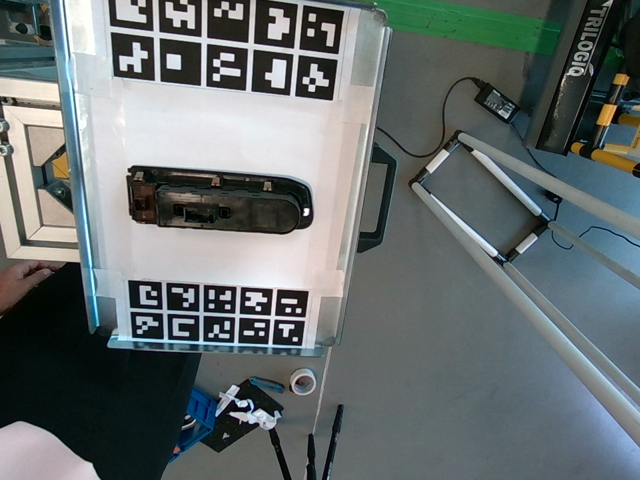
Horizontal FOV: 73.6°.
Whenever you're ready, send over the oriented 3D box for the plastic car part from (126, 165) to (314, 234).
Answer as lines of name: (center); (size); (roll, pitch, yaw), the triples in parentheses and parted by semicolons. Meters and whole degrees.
plastic car part: (-0.104, -0.038, 0.455); (0.203, 0.066, 0.067); (2, 17, -8)
